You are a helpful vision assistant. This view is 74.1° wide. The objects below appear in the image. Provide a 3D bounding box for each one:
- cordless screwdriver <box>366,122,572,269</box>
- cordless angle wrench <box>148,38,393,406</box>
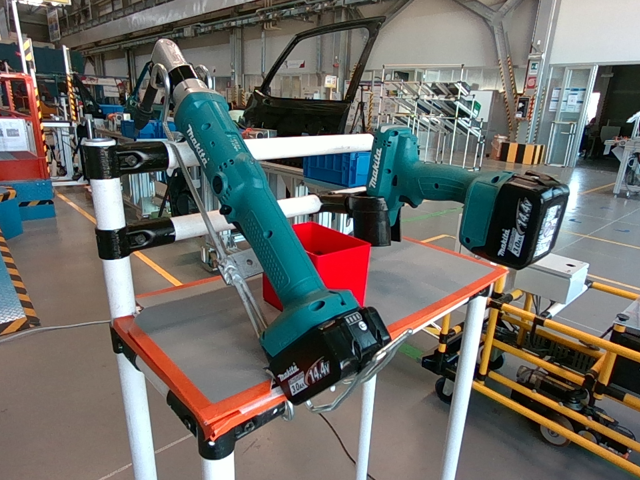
[{"bbox_3d":[0.153,-0.039,0.522,0.074,0.159,0.249,-16,35,-38],"label":"cordless screwdriver"},{"bbox_3d":[-0.082,-0.053,0.426,0.074,0.422,0.098,-12,-25,-46],"label":"cordless angle wrench"}]
